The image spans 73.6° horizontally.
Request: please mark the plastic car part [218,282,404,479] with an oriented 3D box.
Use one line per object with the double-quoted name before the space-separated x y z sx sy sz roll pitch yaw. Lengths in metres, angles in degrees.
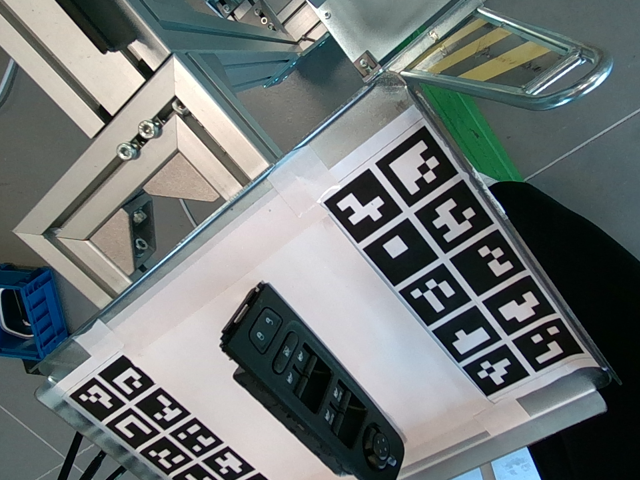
"plastic car part" -0.008 0.132 0.342 0.067 0.202 0.066 -33 18 33
